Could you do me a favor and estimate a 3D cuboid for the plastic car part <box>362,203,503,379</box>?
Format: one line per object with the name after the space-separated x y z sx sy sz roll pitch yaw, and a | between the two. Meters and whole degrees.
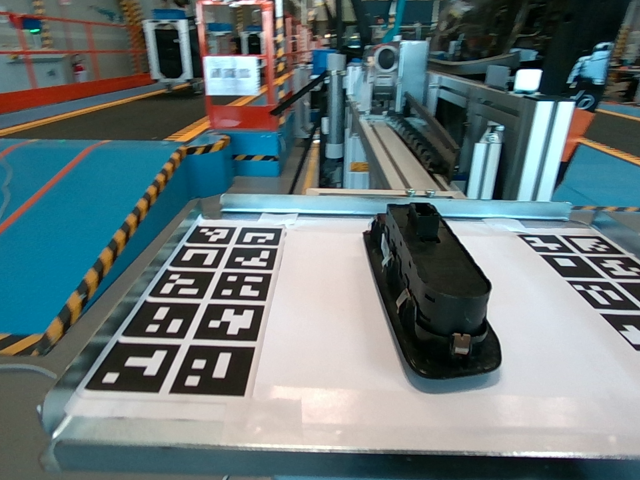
0.077 0.015 0.309 0.066 0.067 0.202 6 28 -4 | plastic car part
